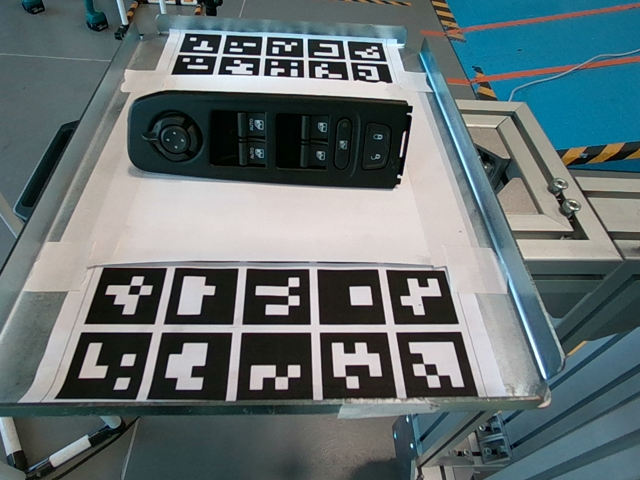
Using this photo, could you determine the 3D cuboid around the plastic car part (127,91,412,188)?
[{"bbox_3d":[-0.040,-0.083,0.323,0.203,0.066,0.067,-1,38,-6],"label":"plastic car part"}]
